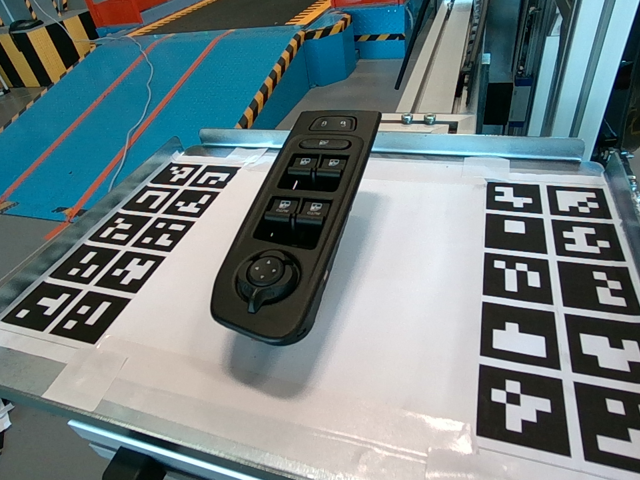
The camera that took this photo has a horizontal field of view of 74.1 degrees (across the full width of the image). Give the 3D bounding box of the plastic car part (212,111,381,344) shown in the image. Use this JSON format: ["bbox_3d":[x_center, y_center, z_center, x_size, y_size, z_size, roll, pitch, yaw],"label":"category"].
[{"bbox_3d":[-0.010,-0.014,0.289,0.066,0.067,0.202,11,47,12],"label":"plastic car part"}]
